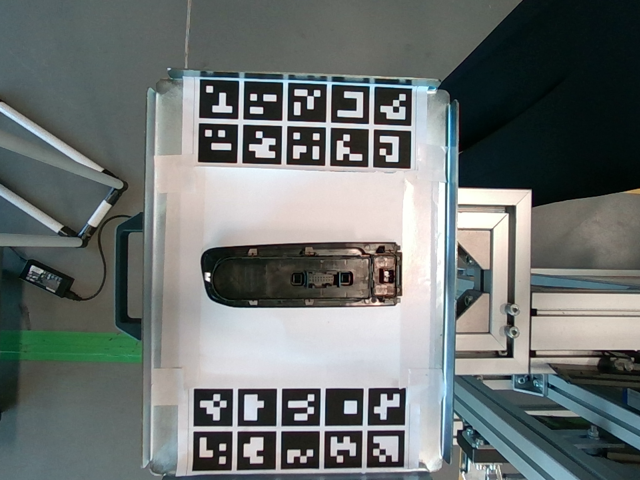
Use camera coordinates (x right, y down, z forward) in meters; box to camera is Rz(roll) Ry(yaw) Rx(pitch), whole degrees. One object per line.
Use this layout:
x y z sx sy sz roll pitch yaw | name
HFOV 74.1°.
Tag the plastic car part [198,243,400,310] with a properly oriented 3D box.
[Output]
-0.019 0.039 0.412 0.203 0.066 0.067 0 6 -1 | plastic car part
